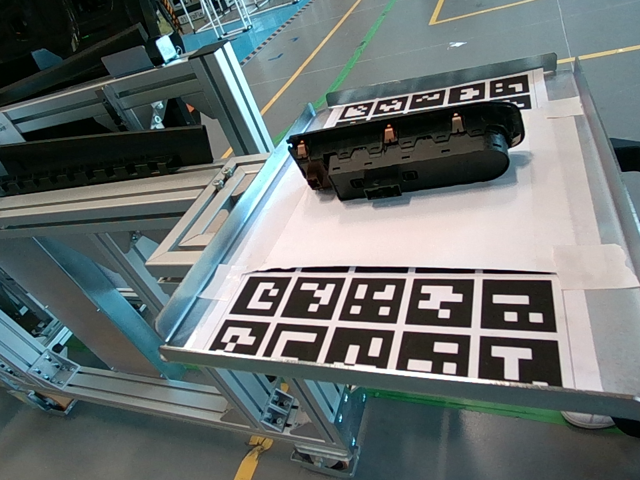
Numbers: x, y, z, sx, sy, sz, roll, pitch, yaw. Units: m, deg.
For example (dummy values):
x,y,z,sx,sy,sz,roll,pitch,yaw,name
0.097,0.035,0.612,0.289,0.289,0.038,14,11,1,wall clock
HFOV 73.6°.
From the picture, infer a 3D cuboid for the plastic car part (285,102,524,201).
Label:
x,y,z,sx,sy,sz,roll,pitch,yaw,name
0.072,-0.072,0.371,0.204,0.067,0.066,-9,-40,14,plastic car part
